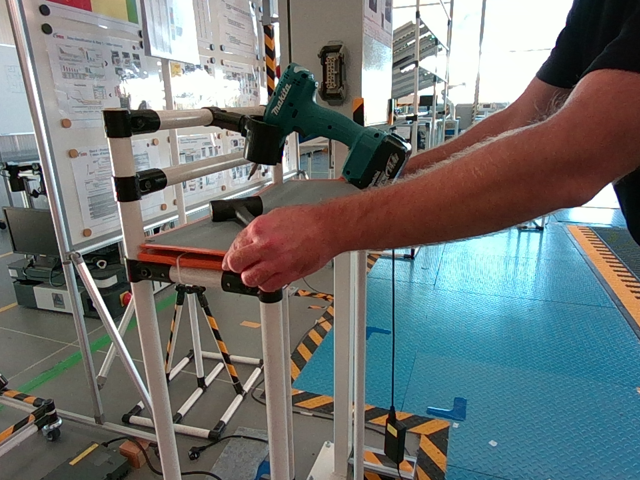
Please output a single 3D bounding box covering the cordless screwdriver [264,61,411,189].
[{"bbox_3d":[0.016,-0.162,0.710,0.249,0.160,0.074,35,32,2],"label":"cordless screwdriver"}]
